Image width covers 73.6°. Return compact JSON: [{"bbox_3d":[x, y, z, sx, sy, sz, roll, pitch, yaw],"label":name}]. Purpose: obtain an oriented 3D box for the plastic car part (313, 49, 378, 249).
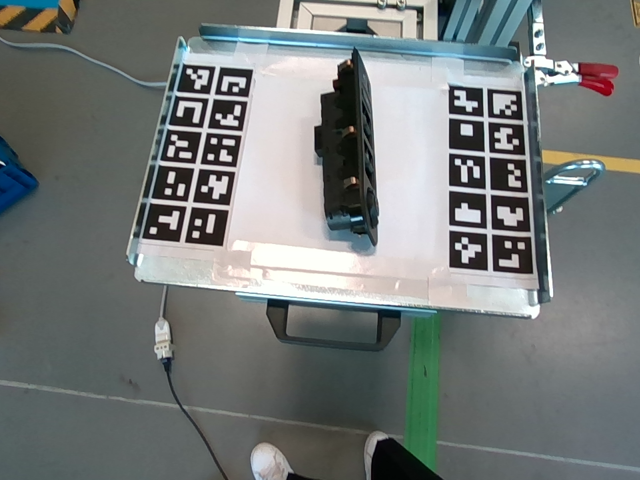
[{"bbox_3d":[0.027,-0.090,0.436,0.067,0.202,0.066,-7,-18,7],"label":"plastic car part"}]
